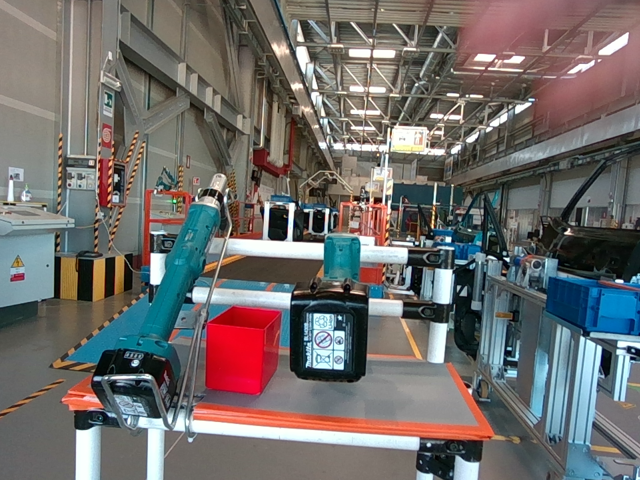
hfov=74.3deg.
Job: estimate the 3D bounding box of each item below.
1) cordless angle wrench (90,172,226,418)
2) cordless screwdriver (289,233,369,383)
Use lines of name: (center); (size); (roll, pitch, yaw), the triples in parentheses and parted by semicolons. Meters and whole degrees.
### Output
cordless angle wrench: (-0.201, 0.036, 0.626); (0.074, 0.421, 0.098); (8, -43, -2)
cordless screwdriver: (0.020, 0.091, 0.509); (0.074, 0.159, 0.248); (2, 12, 6)
